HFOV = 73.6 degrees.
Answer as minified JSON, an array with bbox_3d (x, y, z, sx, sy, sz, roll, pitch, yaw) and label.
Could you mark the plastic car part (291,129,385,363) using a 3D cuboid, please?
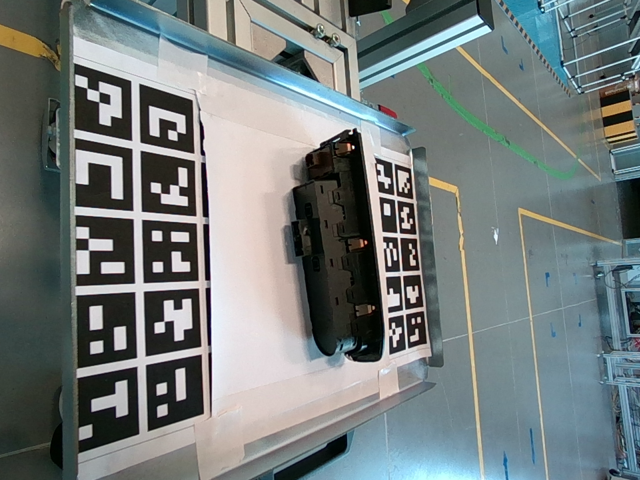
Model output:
[{"bbox_3d":[0.014,0.013,0.367,0.066,0.203,0.067,-13,3,-37],"label":"plastic car part"}]
